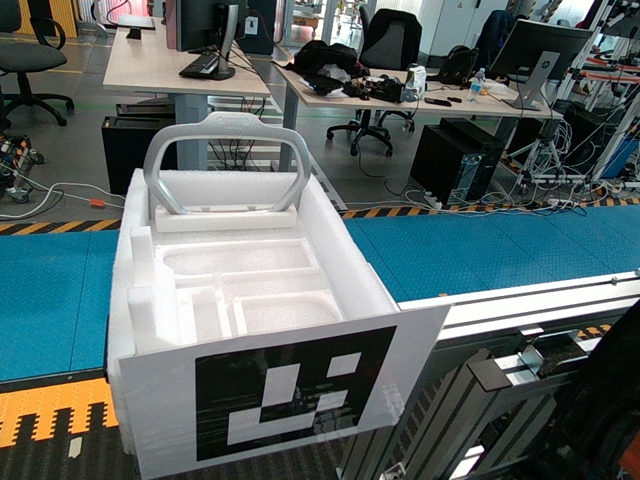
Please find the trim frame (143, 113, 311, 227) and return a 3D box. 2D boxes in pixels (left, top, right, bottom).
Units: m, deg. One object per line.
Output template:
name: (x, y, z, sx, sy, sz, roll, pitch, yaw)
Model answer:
trim frame: (-0.132, -0.098, 0.635, 0.248, 0.184, 0.027, -3, 39, -17)
